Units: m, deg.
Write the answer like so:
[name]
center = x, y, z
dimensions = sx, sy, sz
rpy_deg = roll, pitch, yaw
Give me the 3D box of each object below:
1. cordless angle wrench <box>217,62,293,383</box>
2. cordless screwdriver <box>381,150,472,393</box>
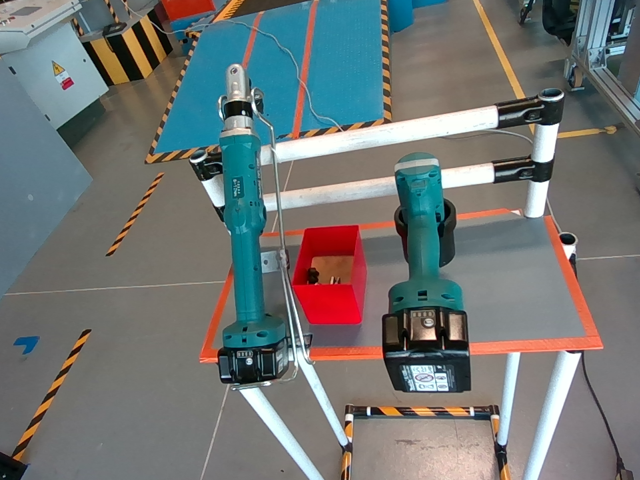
[cordless angle wrench]
center = -0.097, -0.032, 0.566
dimensions = 0.074, 0.422, 0.098
rpy_deg = -6, -4, 12
[cordless screwdriver]
center = 0.117, 0.040, 0.465
dimensions = 0.074, 0.248, 0.159
rpy_deg = -5, -38, 17
